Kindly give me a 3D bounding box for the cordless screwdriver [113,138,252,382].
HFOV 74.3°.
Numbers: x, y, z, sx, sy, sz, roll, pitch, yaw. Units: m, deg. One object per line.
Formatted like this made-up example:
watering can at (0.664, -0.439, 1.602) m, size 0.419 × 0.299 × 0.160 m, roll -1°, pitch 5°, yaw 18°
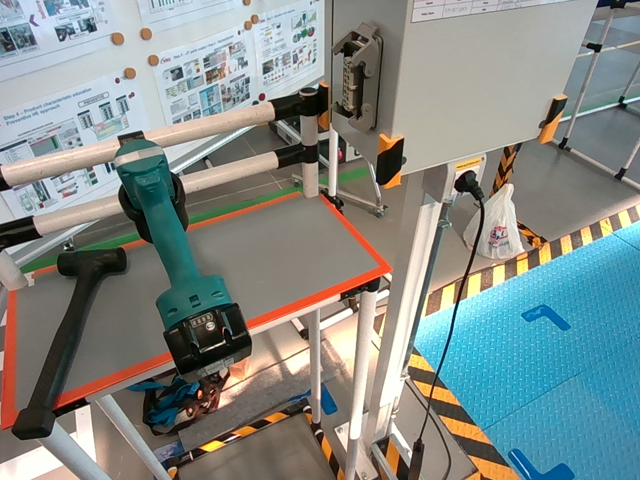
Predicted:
cordless screwdriver at (-0.157, 0.026, 0.475) m, size 0.074 × 0.248 × 0.159 m, roll -21°, pitch -13°, yaw -18°
